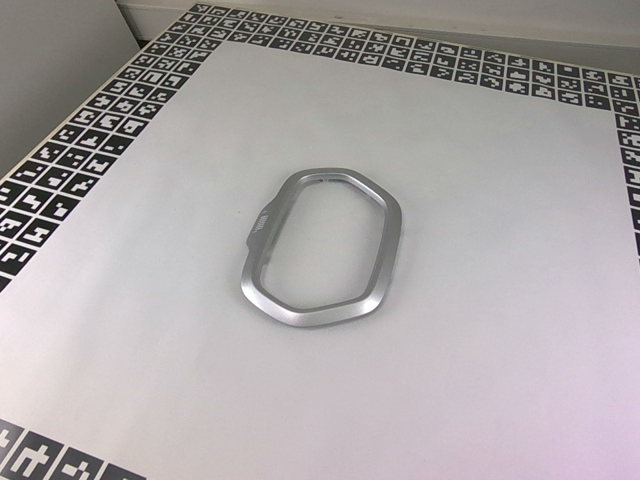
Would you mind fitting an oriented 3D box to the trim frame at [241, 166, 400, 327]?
[{"bbox_3d":[0.001,-0.003,0.532,0.184,0.247,0.027,13,-32,8],"label":"trim frame"}]
